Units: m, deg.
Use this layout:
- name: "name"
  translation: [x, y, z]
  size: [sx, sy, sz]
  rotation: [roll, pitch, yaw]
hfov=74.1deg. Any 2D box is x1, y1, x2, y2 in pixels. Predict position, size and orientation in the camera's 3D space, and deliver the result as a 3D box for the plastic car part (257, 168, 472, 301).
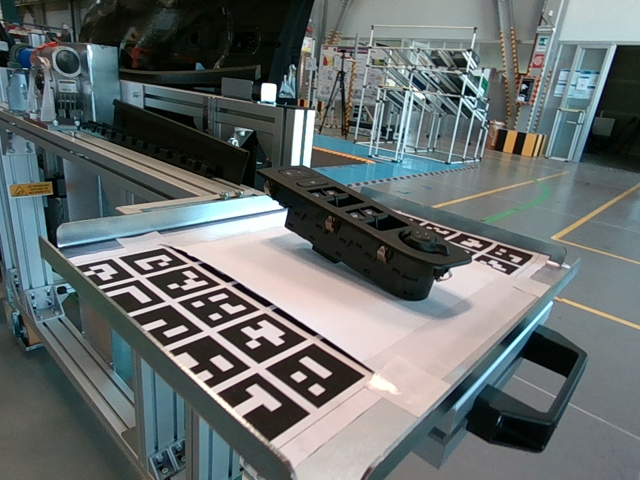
- name: "plastic car part"
  translation: [0.027, -0.007, 0.373]
  size: [0.204, 0.067, 0.066]
  rotation: [27, 20, 34]
